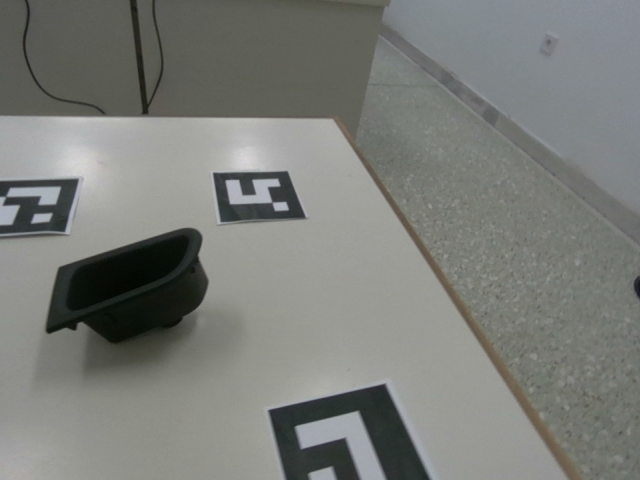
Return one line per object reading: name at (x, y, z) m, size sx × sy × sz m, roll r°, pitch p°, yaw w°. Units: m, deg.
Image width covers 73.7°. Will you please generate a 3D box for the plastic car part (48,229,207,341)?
plastic car part at (-0.141, 0.044, 0.346) m, size 0.116 × 0.066 × 0.071 m, roll -17°, pitch -42°, yaw -8°
